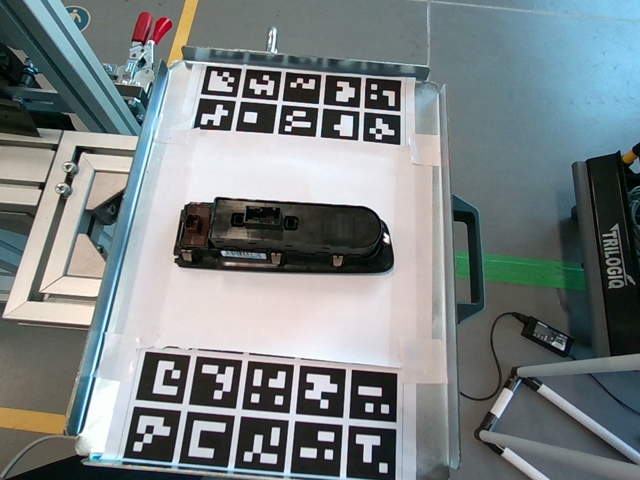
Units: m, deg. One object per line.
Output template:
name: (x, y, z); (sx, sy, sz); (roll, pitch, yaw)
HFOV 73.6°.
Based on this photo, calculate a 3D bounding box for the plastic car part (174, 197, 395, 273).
plastic car part: (-0.030, -0.010, 0.385); (0.203, 0.066, 0.067); (5, -26, -3)
